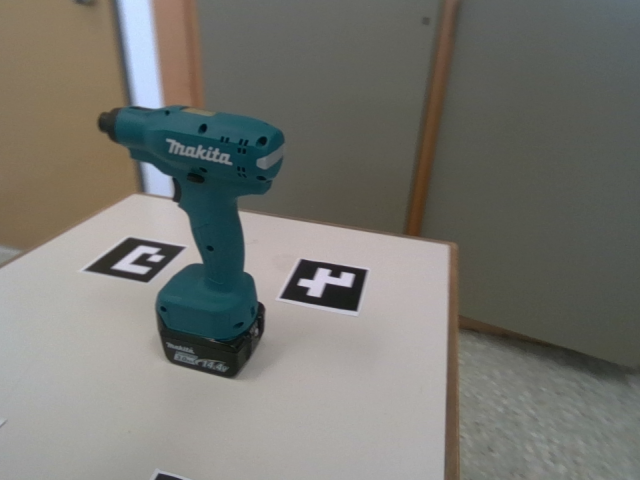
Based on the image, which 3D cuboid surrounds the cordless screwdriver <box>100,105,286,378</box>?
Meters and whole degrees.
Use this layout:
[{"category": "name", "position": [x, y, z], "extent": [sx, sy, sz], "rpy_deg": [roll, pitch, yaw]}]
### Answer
[{"category": "cordless screwdriver", "position": [-0.121, 0.002, 0.399], "extent": [0.160, 0.249, 0.074], "rpy_deg": [14, 29, 12]}]
